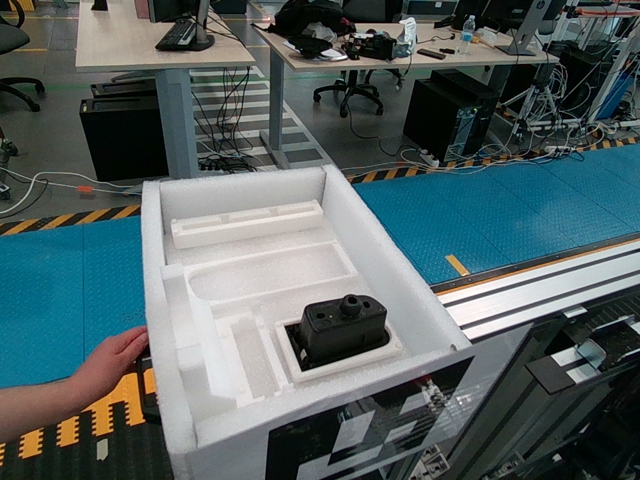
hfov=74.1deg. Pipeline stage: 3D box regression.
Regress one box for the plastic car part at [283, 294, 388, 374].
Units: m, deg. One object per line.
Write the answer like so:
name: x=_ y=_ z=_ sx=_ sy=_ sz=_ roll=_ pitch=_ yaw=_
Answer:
plastic car part: x=0.023 y=0.093 z=0.477 sx=0.116 sy=0.071 sz=0.066 roll=-11 pitch=43 yaw=-18
